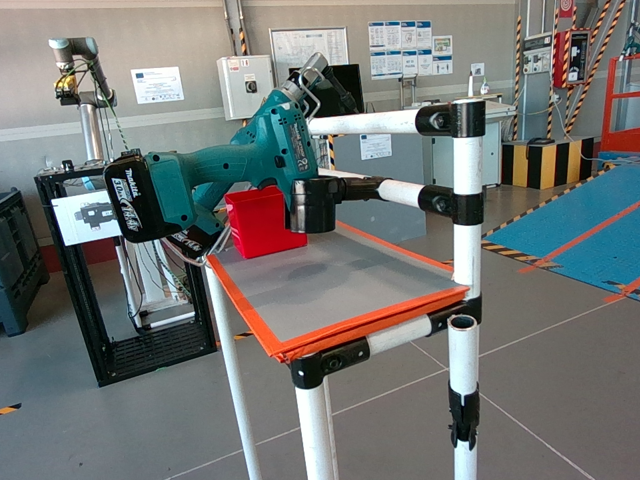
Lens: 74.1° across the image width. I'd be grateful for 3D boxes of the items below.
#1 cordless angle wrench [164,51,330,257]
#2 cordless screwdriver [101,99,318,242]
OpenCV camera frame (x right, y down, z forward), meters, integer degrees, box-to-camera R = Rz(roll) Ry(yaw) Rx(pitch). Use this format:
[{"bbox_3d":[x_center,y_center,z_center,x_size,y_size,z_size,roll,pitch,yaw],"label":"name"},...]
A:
[{"bbox_3d":[-0.122,-0.165,0.742,0.098,0.422,0.074,40,-5,-31],"label":"cordless angle wrench"},{"bbox_3d":[-0.119,-0.062,0.519,0.248,0.159,0.074,-22,22,-19],"label":"cordless screwdriver"}]
